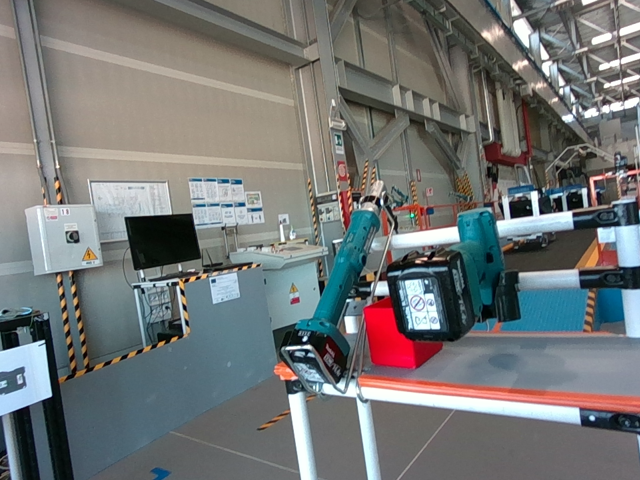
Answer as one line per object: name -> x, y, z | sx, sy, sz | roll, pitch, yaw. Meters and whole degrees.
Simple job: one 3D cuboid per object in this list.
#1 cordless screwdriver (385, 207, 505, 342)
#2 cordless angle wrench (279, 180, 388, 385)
cordless screwdriver -> 0.180, 0.058, 0.531 | 0.074, 0.159, 0.248 | -9, 9, 38
cordless angle wrench -> 0.054, 0.040, 0.749 | 0.074, 0.421, 0.098 | -2, -43, 33
